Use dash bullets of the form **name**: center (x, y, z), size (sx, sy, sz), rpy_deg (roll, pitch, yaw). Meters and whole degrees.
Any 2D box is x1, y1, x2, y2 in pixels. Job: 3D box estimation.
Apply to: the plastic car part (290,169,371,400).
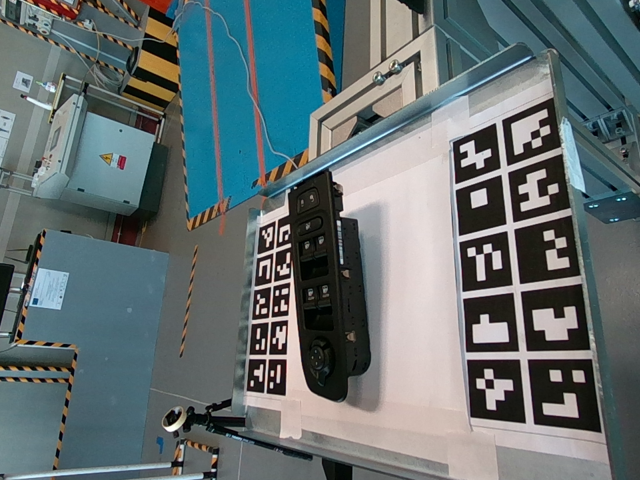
- **plastic car part**: center (0.011, 0.042, 0.401), size (0.067, 0.202, 0.067), rpy_deg (-16, -21, 41)
